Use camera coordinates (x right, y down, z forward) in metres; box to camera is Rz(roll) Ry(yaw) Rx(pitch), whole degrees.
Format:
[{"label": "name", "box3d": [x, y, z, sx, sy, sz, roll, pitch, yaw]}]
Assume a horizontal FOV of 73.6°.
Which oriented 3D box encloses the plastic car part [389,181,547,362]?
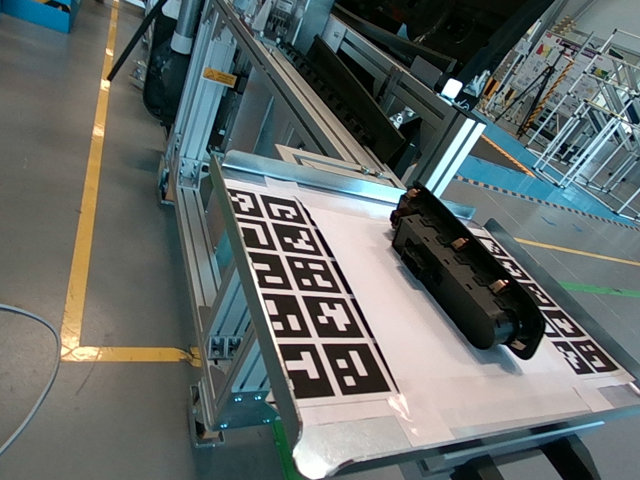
[{"label": "plastic car part", "box3d": [0.124, 0.026, 0.408, 0.067, 0.066, 0.203, -8, 45, -34]}]
